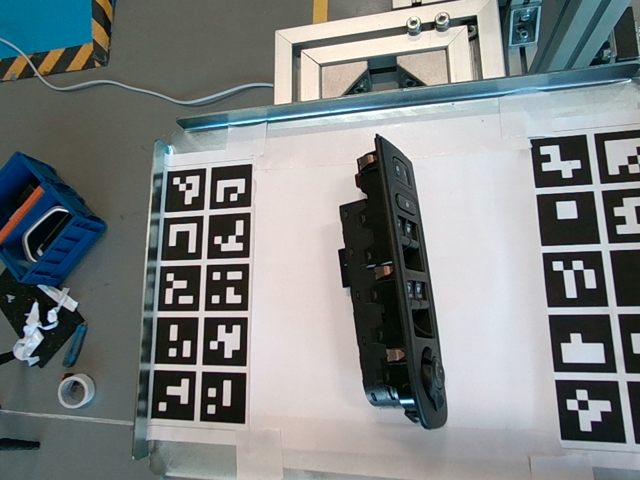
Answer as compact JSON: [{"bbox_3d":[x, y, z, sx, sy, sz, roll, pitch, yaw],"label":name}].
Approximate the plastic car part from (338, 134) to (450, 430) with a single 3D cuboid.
[{"bbox_3d":[0.049,0.032,0.306,0.067,0.202,0.066,-17,-15,23],"label":"plastic car part"}]
